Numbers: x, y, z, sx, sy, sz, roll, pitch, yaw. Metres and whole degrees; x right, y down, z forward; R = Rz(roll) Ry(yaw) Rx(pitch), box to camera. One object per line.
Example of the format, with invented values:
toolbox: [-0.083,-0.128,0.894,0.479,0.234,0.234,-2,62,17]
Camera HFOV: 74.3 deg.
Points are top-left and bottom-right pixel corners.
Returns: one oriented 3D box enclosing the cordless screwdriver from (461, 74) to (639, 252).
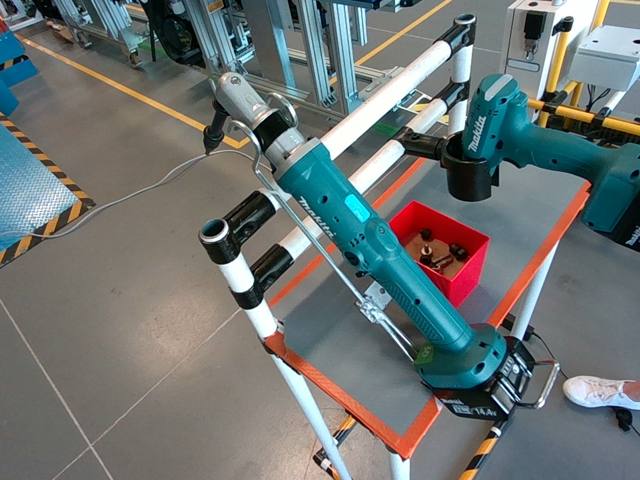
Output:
cordless screwdriver: [0.276,-0.075,0.490,0.248,0.074,0.159,37,-24,26]

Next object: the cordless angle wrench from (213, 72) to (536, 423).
cordless angle wrench: [0.045,0.004,0.421,0.074,0.423,0.098,-45,7,-31]
